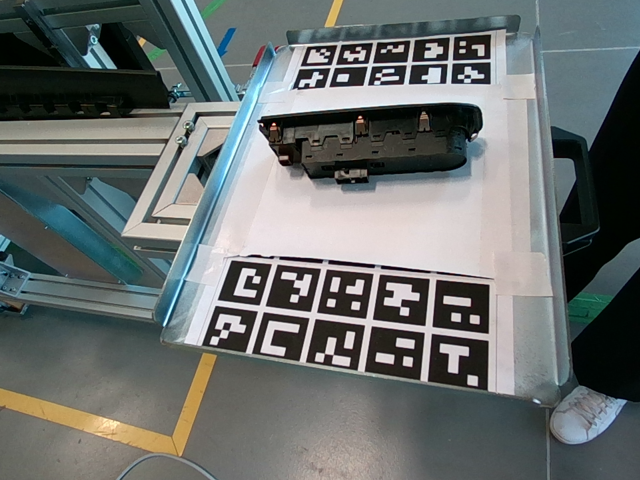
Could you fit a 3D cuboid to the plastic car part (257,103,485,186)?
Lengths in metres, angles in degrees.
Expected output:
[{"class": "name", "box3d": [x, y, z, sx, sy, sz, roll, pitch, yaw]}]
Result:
[{"class": "plastic car part", "box3d": [0.048, -0.086, 0.385, 0.203, 0.067, 0.066, -6, -20, 9]}]
